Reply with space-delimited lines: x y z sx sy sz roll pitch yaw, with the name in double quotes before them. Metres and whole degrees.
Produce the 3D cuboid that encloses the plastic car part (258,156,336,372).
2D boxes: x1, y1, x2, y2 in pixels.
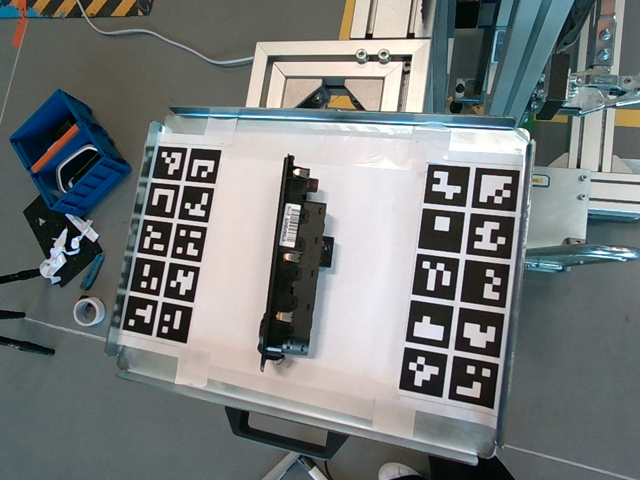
"plastic car part" -0.023 0.026 0.420 0.067 0.203 0.067 12 -7 -10
